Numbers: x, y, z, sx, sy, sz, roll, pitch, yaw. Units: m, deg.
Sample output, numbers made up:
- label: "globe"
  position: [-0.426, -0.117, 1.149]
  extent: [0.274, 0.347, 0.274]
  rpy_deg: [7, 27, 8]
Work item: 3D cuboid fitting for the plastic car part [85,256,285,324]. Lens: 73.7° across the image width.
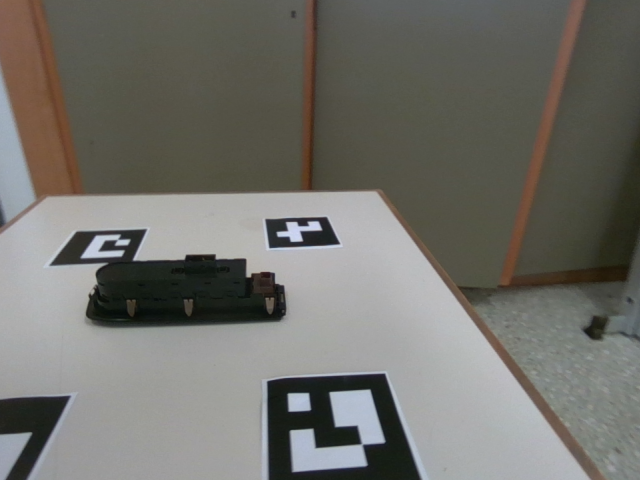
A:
- label: "plastic car part"
  position: [-0.139, 0.051, 0.438]
  extent: [0.202, 0.067, 0.066]
  rpy_deg: [-5, 32, -5]
